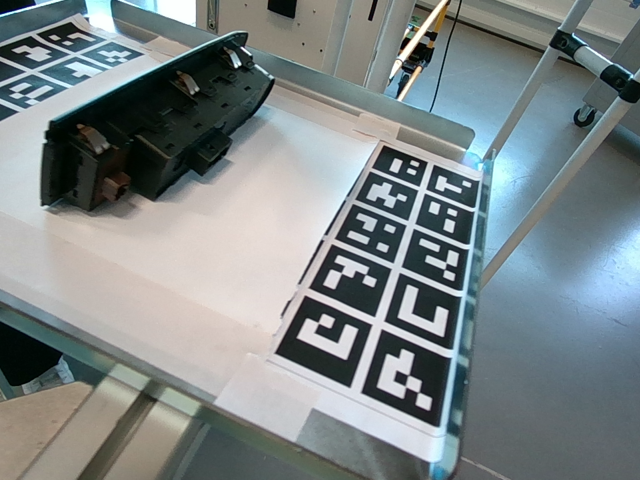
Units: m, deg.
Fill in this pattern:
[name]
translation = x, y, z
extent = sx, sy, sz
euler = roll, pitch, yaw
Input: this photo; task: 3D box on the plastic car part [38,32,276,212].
[plastic car part]
translation = -0.086, -0.085, 0.287
extent = 0.067, 0.202, 0.066
euler = 29, -44, -2
